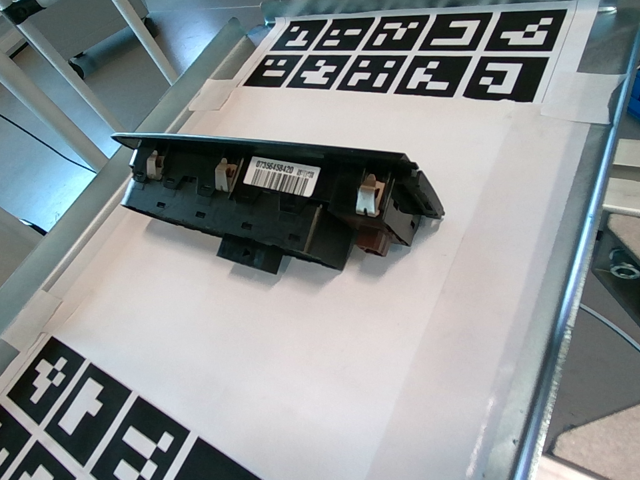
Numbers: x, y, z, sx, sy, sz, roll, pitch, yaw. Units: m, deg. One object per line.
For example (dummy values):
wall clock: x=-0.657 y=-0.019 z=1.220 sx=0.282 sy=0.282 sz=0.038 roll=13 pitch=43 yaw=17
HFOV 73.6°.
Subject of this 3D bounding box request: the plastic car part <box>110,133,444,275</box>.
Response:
plastic car part: x=-0.042 y=-0.021 z=0.237 sx=0.204 sy=0.067 sz=0.066 roll=17 pitch=-1 yaw=30
